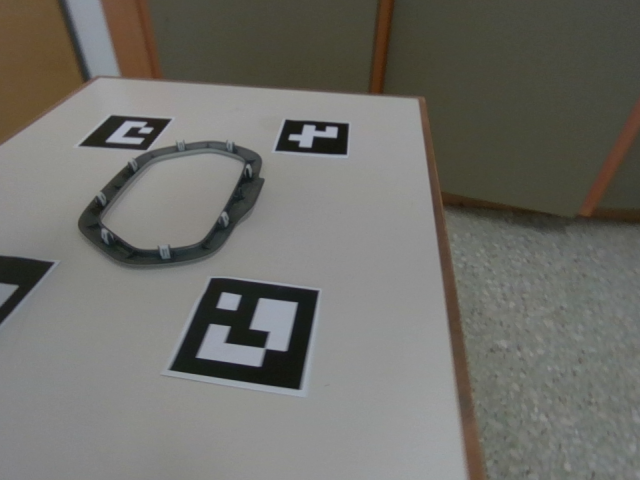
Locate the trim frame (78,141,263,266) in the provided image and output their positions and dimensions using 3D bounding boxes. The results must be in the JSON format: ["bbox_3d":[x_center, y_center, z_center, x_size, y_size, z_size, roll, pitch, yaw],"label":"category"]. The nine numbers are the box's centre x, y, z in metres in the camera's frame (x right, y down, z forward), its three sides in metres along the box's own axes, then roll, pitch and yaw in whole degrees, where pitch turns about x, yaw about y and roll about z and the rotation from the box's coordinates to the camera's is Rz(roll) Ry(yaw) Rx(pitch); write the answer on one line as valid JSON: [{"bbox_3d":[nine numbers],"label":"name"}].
[{"bbox_3d":[-0.160,-0.058,0.494,0.184,0.027,0.248,7,39,5],"label":"trim frame"}]
